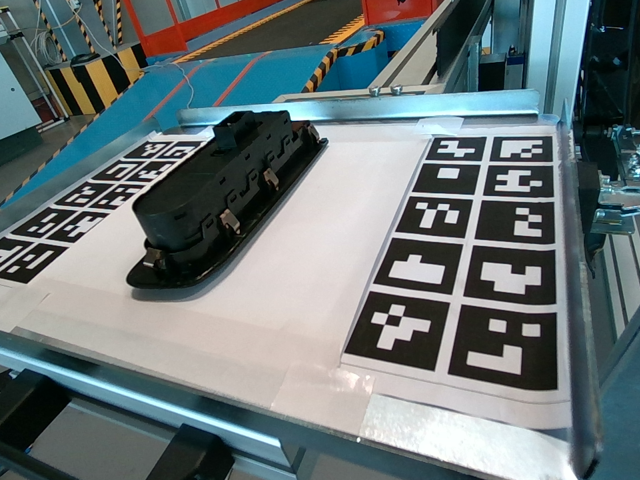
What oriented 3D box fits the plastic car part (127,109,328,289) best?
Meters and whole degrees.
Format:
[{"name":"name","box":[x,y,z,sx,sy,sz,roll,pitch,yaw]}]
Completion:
[{"name":"plastic car part","box":[-0.058,-0.046,0.298,0.066,0.067,0.202,9,44,19]}]
